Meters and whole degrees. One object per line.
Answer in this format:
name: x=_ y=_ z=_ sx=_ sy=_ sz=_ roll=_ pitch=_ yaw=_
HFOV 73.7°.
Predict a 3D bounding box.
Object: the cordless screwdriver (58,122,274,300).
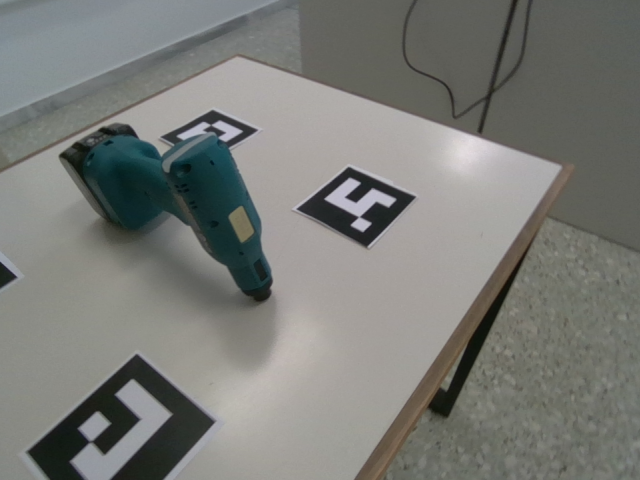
cordless screwdriver: x=-0.148 y=-0.032 z=0.421 sx=0.251 sy=0.158 sz=0.074 roll=17 pitch=50 yaw=40
